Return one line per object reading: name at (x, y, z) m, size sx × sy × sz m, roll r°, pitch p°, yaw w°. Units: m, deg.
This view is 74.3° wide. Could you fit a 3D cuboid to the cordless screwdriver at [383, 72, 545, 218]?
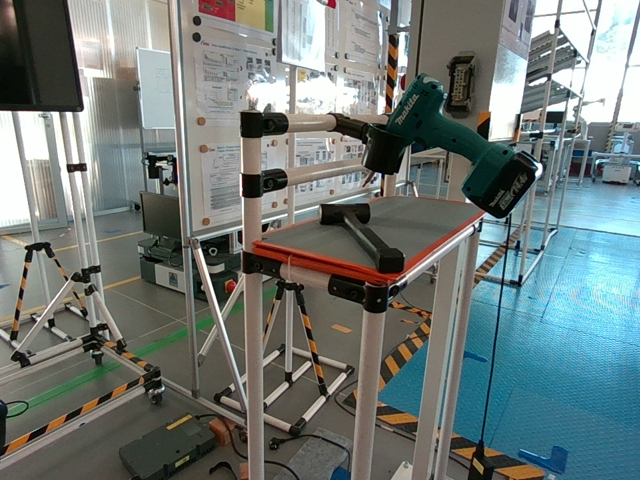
cordless screwdriver at (0.210, -0.131, 0.677) m, size 0.248 × 0.160 × 0.074 m, roll 43°, pitch 38°, yaw 15°
